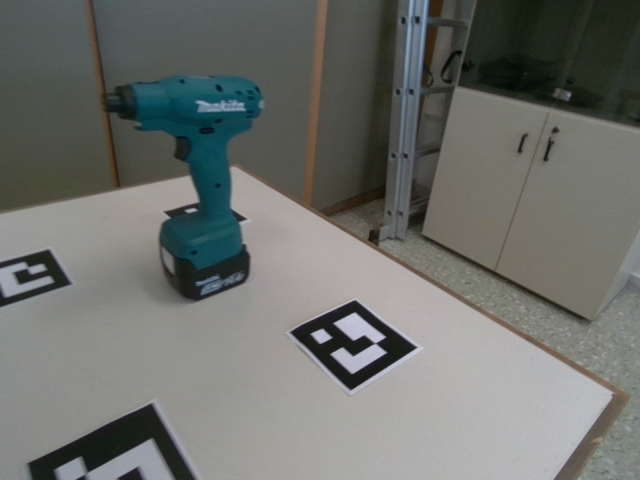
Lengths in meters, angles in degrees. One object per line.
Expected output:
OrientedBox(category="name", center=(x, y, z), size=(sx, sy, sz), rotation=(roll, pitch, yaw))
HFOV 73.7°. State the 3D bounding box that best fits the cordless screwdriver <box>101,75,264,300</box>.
OrientedBox(category="cordless screwdriver", center=(-0.148, -0.052, 0.476), size=(0.157, 0.249, 0.075), rotation=(-15, 35, -38))
